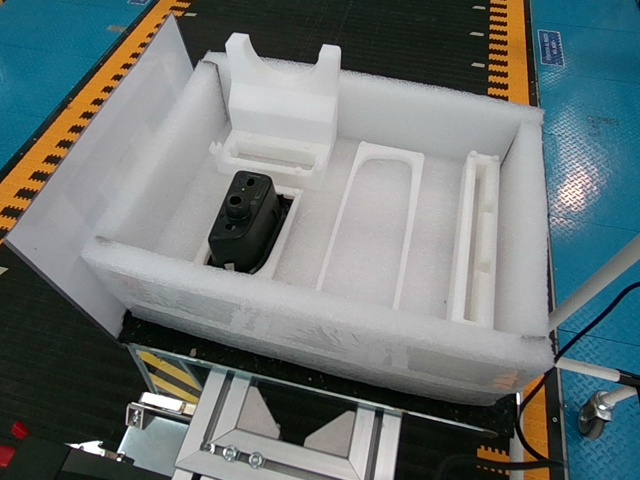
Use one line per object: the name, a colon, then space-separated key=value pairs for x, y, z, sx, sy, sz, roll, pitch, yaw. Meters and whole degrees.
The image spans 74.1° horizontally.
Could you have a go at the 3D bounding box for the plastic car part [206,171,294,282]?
plastic car part: x=-0.075 y=-0.022 z=0.421 sx=0.066 sy=0.116 sz=0.071 roll=12 pitch=-36 yaw=10
